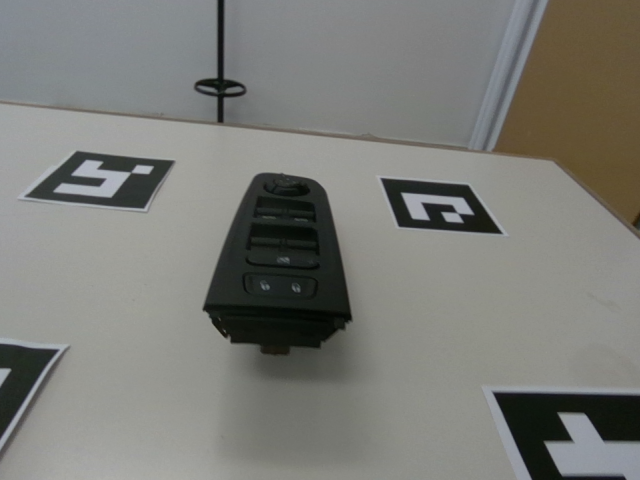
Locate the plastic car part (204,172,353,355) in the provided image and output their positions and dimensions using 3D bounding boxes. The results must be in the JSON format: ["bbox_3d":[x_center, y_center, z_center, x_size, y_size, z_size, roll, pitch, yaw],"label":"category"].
[{"bbox_3d":[-0.022,0.007,0.284,0.066,0.067,0.203,-1,31,-2],"label":"plastic car part"}]
